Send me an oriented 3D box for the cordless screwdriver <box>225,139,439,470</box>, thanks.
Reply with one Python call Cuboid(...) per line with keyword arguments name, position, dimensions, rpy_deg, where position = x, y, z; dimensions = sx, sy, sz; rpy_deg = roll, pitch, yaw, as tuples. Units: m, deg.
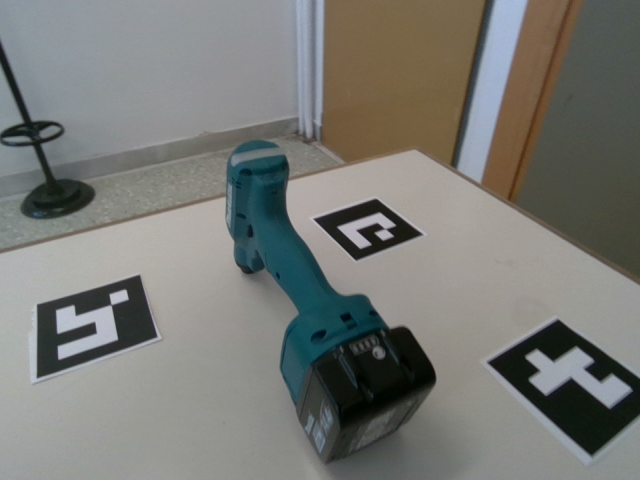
Cuboid(name="cordless screwdriver", position=(-0.020, 0.051, 0.356), dimensions=(0.074, 0.250, 0.159), rpy_deg=(-15, -36, -24))
